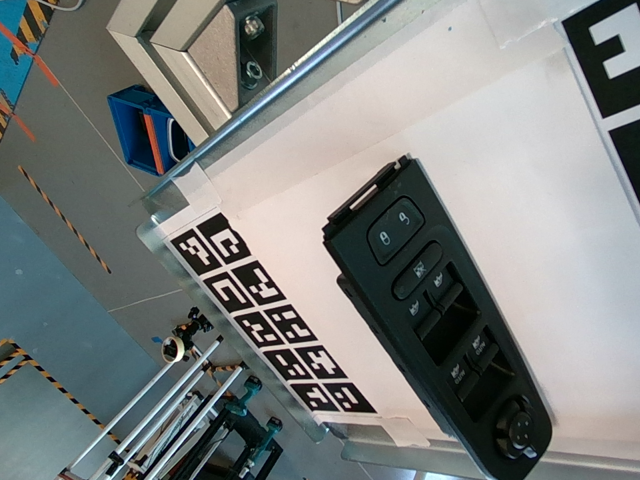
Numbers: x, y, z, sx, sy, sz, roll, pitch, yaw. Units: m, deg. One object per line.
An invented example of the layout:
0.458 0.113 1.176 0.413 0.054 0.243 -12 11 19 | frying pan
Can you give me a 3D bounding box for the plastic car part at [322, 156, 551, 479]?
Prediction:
0.064 0.060 0.242 0.066 0.203 0.067 -45 16 -31 | plastic car part
